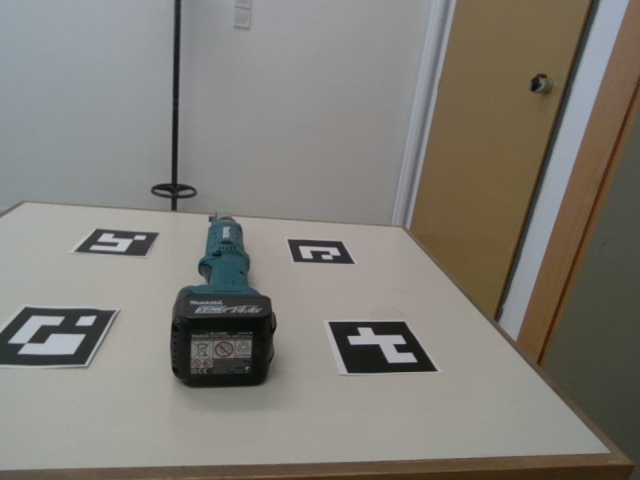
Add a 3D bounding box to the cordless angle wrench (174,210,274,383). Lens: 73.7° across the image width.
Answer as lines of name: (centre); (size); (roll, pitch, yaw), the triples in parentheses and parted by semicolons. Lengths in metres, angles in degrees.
cordless angle wrench: (-0.133, 0.031, 0.593); (0.097, 0.074, 0.424); (3, 20, -14)
